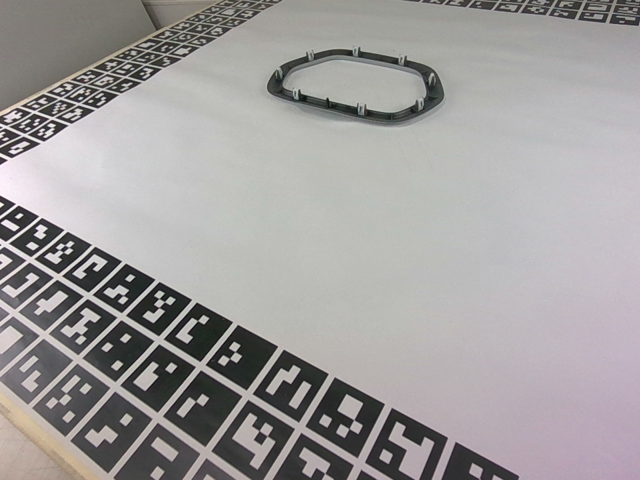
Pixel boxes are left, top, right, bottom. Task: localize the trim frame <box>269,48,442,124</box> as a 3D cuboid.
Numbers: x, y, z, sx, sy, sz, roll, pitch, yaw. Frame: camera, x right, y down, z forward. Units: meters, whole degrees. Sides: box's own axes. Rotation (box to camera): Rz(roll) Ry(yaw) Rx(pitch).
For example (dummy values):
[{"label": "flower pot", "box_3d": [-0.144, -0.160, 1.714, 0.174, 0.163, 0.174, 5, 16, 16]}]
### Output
[{"label": "trim frame", "box_3d": [0.047, -0.221, 0.590, 0.249, 0.027, 0.183, 24, 54, 22]}]
